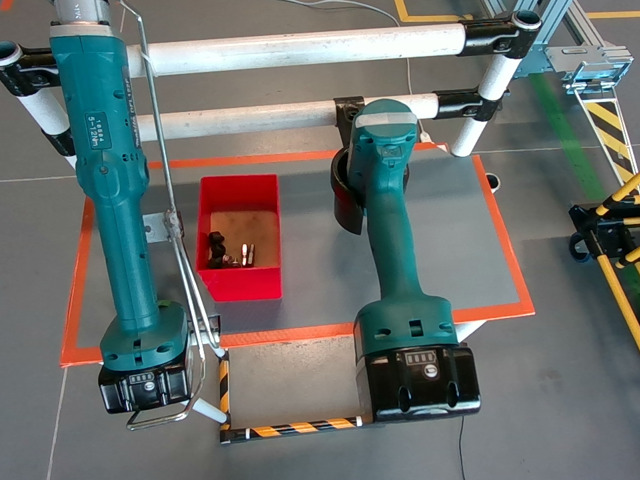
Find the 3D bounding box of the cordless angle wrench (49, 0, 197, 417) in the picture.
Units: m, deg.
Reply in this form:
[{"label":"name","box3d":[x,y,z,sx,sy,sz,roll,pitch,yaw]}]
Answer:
[{"label":"cordless angle wrench","box3d":[-0.176,-0.057,0.364,0.074,0.423,0.098,-7,14,-10]}]

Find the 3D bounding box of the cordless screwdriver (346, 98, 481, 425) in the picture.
[{"label":"cordless screwdriver","box3d":[0.059,0.025,0.369,0.074,0.248,0.159,-4,-19,-2]}]
